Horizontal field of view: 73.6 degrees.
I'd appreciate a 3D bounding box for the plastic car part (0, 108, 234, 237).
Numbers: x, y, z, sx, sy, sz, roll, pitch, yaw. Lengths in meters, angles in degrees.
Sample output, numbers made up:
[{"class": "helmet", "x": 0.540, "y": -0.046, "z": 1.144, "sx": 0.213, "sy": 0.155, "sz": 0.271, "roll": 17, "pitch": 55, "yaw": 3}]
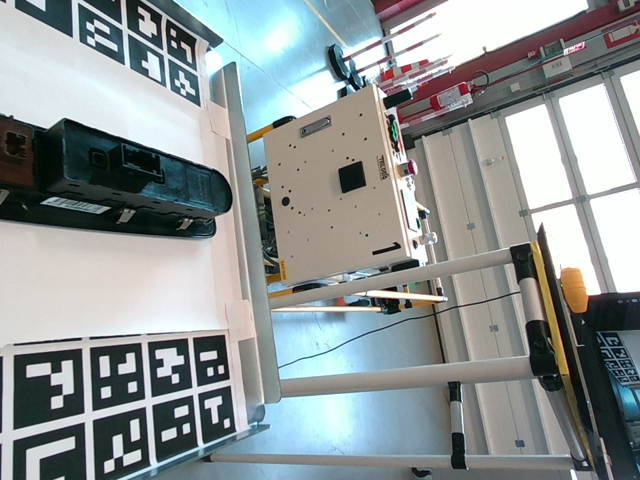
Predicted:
[{"class": "plastic car part", "x": -0.136, "y": -0.044, "z": 0.312, "sx": 0.067, "sy": 0.066, "sz": 0.202, "roll": -22, "pitch": -16, "yaw": 23}]
